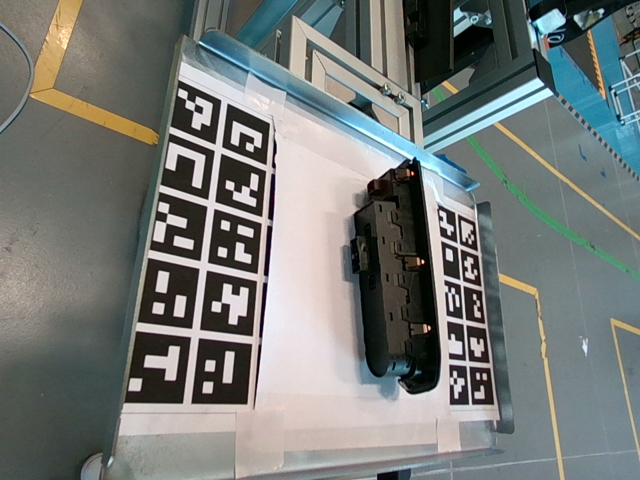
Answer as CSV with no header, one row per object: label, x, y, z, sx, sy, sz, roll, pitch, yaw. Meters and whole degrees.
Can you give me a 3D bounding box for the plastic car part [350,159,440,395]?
plastic car part,0.063,0.032,0.372,0.067,0.202,0.067,0,-14,-30
